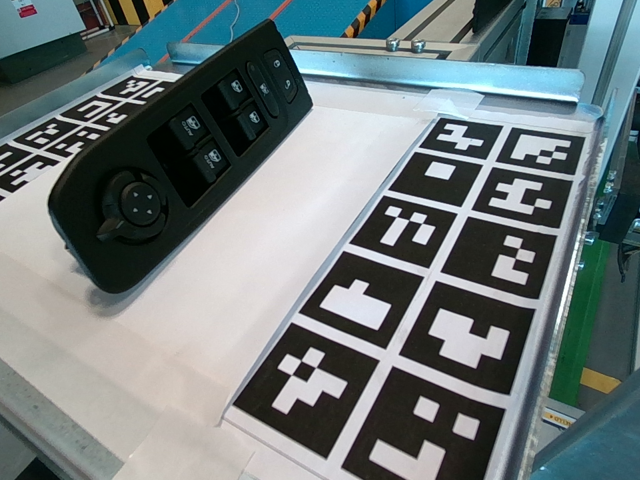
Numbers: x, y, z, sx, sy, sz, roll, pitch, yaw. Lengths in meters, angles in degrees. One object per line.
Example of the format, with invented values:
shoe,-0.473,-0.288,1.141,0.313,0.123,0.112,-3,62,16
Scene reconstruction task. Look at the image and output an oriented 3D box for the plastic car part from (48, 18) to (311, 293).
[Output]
plastic car part,-0.078,-0.059,0.250,0.067,0.066,0.202,1,42,27
